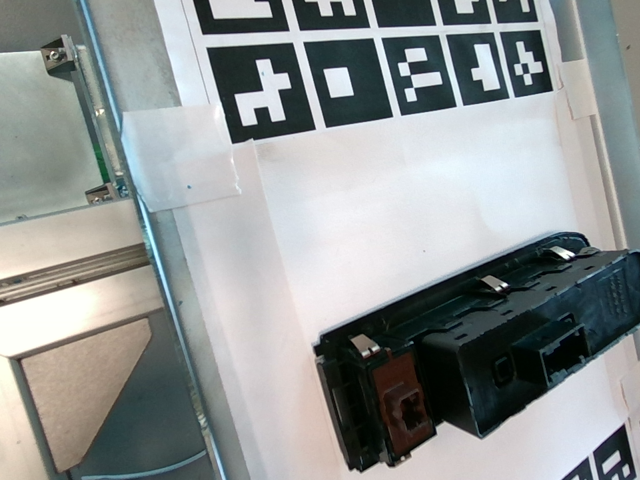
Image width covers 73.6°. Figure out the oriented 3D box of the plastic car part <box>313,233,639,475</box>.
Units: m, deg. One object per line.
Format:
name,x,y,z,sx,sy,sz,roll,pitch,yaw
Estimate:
plastic car part,0.100,0.042,0.211,0.202,0.066,0.067,-18,-2,-30
